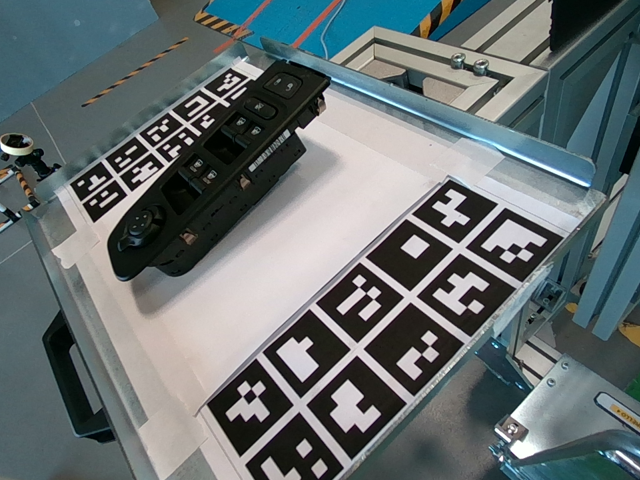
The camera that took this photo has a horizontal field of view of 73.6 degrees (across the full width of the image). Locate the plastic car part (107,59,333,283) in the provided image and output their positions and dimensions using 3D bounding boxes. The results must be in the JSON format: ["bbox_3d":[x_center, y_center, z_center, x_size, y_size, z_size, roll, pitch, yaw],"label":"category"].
[{"bbox_3d":[-0.073,-0.046,0.325,0.066,0.202,0.067,40,-11,30],"label":"plastic car part"}]
